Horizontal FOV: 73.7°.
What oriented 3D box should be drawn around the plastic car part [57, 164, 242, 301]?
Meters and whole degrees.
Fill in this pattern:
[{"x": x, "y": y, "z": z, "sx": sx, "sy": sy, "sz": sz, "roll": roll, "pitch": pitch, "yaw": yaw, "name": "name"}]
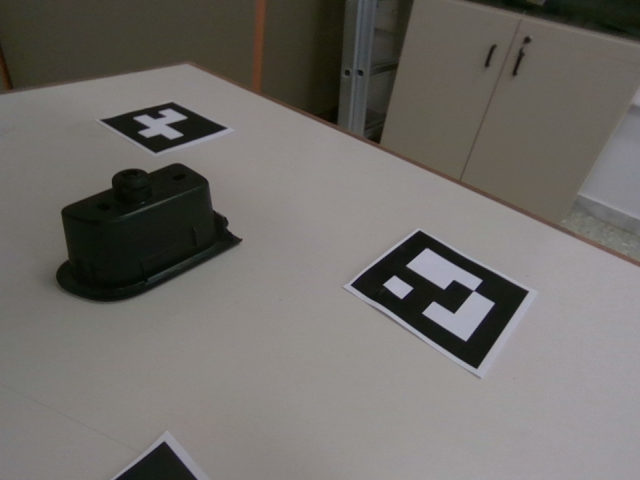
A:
[{"x": -0.117, "y": -0.015, "z": 0.289, "sx": 0.066, "sy": 0.071, "sz": 0.115, "roll": 30, "pitch": 39, "yaw": 27, "name": "plastic car part"}]
